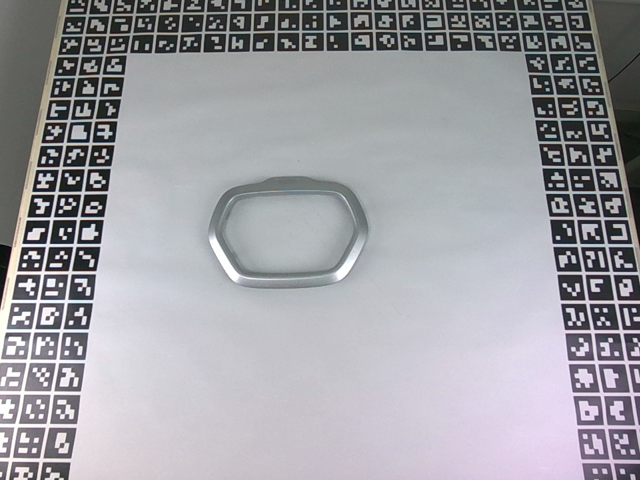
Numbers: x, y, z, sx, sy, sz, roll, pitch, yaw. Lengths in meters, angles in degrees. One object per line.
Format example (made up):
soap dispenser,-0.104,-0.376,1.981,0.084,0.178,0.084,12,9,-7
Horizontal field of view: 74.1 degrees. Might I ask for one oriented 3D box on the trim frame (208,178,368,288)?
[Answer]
trim frame,-0.050,-0.016,0.659,0.249,0.184,0.027,-3,-16,3
